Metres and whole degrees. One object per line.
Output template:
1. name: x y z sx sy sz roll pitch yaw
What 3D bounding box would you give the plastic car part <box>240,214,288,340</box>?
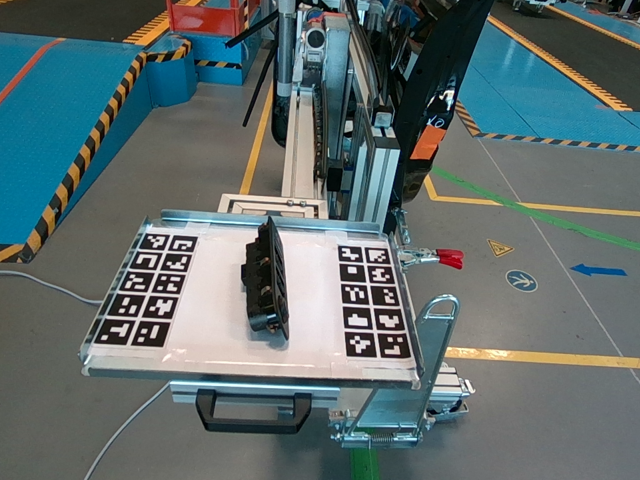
1. plastic car part: -0.079 0.050 0.595 0.067 0.066 0.203 -12 41 -5
